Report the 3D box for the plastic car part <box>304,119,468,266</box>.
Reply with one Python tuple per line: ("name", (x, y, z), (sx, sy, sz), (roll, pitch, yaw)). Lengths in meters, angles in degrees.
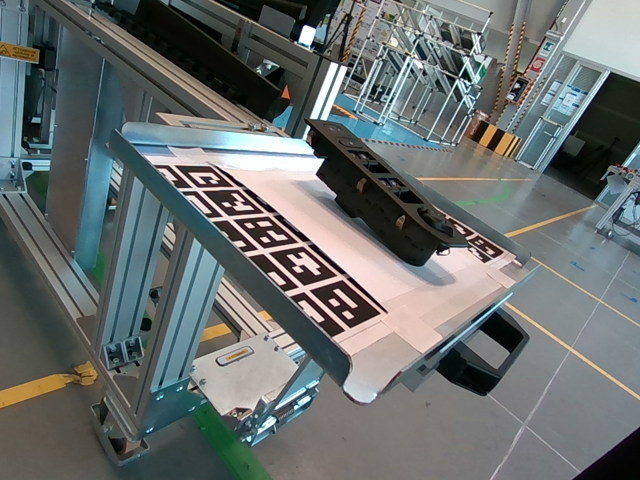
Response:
("plastic car part", (0.055, -0.046, 0.433), (0.203, 0.067, 0.066), (43, 22, 26))
